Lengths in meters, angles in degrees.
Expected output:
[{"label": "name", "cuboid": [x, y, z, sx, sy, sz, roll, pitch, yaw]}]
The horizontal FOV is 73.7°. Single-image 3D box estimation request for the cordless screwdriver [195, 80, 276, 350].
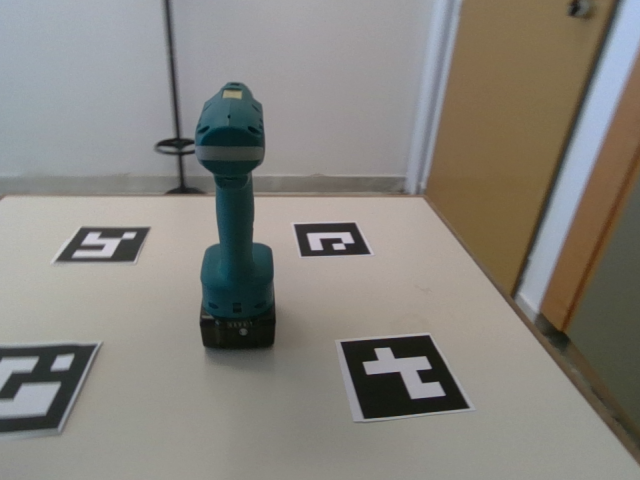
[{"label": "cordless screwdriver", "cuboid": [-0.080, -0.022, 0.419, 0.074, 0.249, 0.159, 0, 34, -8]}]
